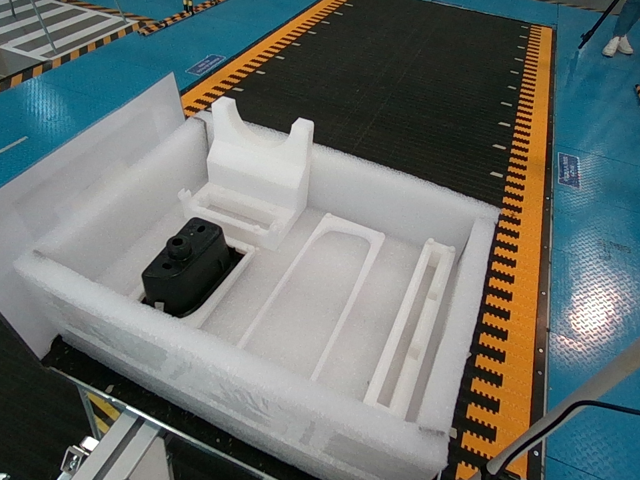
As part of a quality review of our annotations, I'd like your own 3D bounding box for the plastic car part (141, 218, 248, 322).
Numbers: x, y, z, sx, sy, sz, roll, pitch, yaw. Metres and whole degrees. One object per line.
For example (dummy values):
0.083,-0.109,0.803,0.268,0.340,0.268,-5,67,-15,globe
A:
-0.133,0.022,0.431,0.066,0.071,0.116,20,45,15,plastic car part
